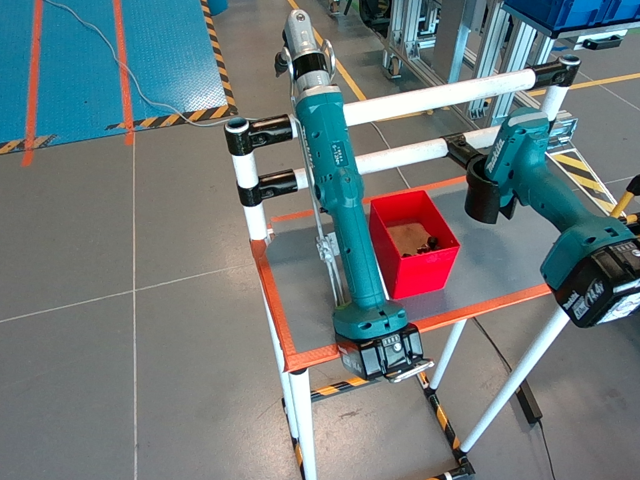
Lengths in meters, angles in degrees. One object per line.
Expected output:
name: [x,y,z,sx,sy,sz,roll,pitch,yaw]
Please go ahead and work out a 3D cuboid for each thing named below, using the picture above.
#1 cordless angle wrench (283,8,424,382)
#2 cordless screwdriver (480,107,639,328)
cordless angle wrench: [0.021,-0.058,0.488,0.074,0.423,0.098,-14,1,-18]
cordless screwdriver: [0.267,-0.018,0.495,0.074,0.248,0.160,-12,-34,-8]
